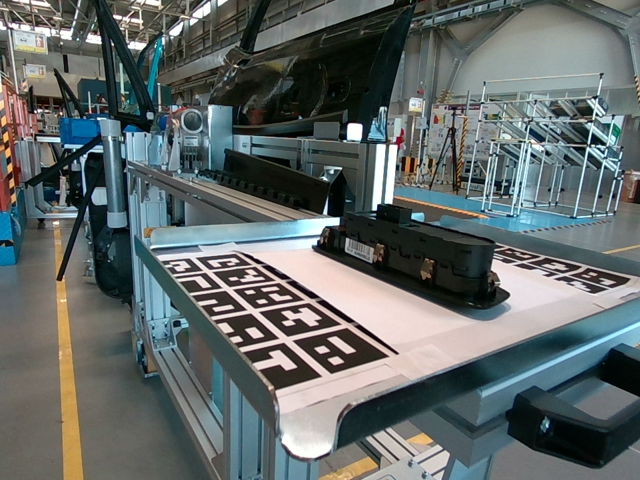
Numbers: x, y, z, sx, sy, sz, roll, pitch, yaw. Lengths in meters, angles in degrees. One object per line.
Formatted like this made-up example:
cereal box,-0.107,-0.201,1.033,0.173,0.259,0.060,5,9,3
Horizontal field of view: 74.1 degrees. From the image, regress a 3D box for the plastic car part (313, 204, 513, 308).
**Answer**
plastic car part,0.078,0.006,0.380,0.066,0.067,0.204,2,15,-36
